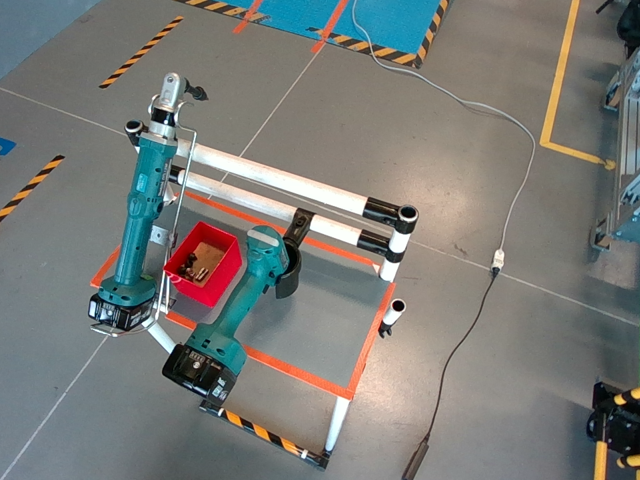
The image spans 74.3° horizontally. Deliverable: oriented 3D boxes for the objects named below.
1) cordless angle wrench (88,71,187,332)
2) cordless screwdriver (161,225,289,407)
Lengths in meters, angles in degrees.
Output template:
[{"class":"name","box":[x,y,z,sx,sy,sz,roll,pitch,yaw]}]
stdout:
[{"class":"cordless angle wrench","box":[-0.283,-0.060,0.691,0.074,0.423,0.098,19,11,7]},{"class":"cordless screwdriver","box":[-0.118,0.112,0.625,0.074,0.248,0.159,22,-22,13]}]
